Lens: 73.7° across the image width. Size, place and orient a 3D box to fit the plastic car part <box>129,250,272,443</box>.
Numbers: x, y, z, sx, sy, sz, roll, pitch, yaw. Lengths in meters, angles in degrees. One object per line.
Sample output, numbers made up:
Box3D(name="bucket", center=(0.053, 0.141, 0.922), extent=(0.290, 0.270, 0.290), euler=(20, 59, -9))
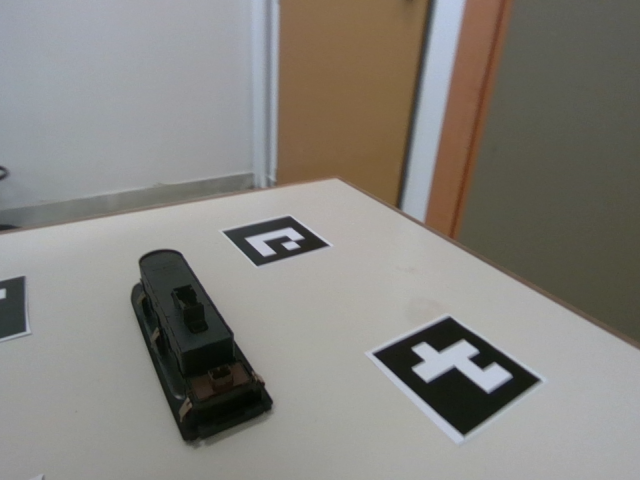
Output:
Box3D(name="plastic car part", center=(-0.117, 0.066, 0.358), extent=(0.066, 0.067, 0.205), euler=(-20, 32, -27))
